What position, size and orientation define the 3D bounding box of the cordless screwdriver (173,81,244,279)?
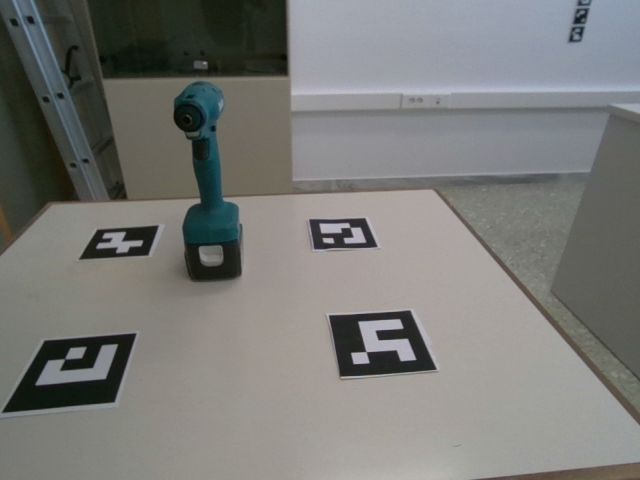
[{"bbox_3d":[-0.143,-0.064,0.540,0.074,0.248,0.159,-2,25,-5],"label":"cordless screwdriver"}]
